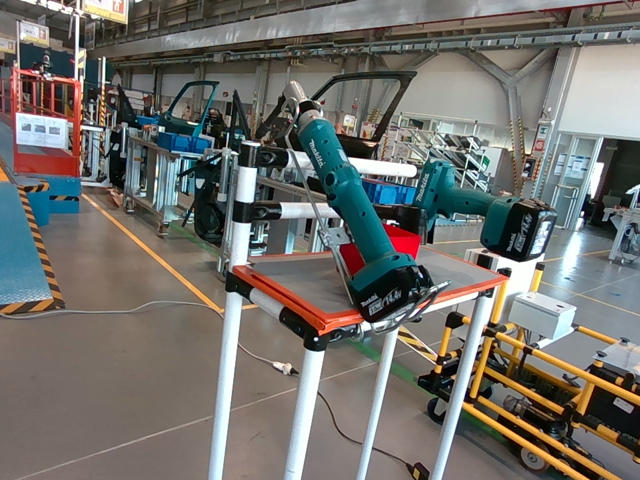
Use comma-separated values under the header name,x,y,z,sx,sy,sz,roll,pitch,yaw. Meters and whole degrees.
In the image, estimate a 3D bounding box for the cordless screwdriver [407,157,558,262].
name,x,y,z,sx,sy,sz,roll,pitch,yaw
cordless screwdriver,0.261,-0.033,0.737,0.074,0.159,0.248,-4,28,-40

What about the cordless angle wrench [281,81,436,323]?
name,x,y,z,sx,sy,sz,roll,pitch,yaw
cordless angle wrench,0.031,-0.085,0.644,0.074,0.422,0.098,0,-32,-48
